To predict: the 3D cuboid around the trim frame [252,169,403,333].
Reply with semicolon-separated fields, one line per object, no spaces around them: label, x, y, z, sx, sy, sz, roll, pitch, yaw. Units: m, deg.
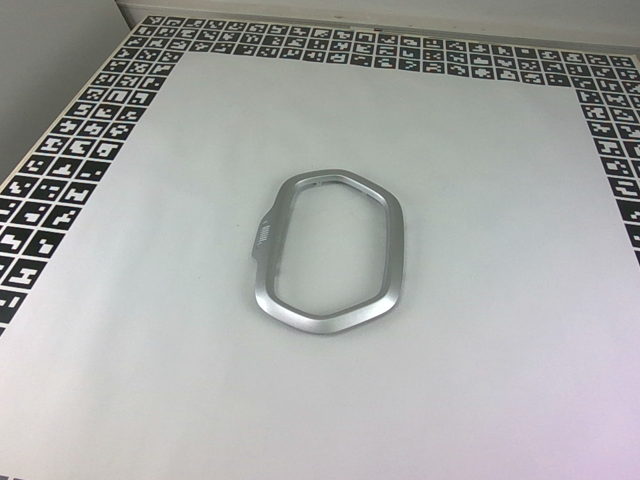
trim frame;0.009;0.001;0.525;0.184;0.247;0.027;6;-34;4
